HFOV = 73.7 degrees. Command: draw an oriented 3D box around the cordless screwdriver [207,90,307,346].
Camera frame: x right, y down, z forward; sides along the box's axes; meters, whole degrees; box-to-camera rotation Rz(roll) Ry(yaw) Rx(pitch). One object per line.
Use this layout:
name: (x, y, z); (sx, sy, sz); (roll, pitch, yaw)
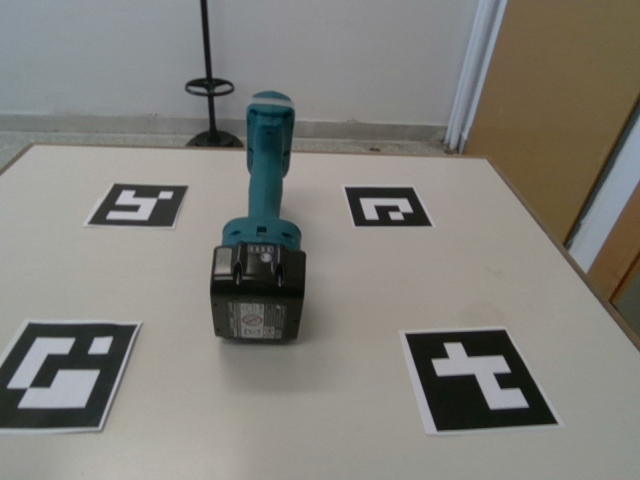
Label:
cordless screwdriver: (-0.058, -0.014, 0.430); (0.074, 0.249, 0.159); (4, -38, -7)
